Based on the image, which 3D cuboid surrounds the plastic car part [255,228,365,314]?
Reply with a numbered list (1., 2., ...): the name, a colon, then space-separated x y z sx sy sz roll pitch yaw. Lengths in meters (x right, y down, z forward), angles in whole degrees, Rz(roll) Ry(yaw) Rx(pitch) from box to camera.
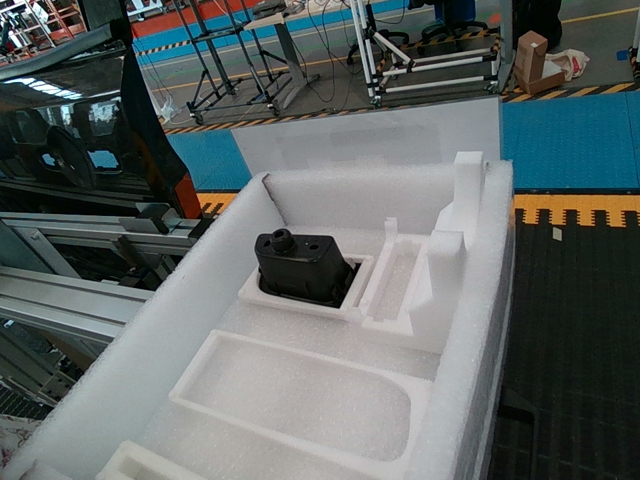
1. plastic car part: -0.024 0.021 0.431 0.117 0.071 0.065 8 45 29
